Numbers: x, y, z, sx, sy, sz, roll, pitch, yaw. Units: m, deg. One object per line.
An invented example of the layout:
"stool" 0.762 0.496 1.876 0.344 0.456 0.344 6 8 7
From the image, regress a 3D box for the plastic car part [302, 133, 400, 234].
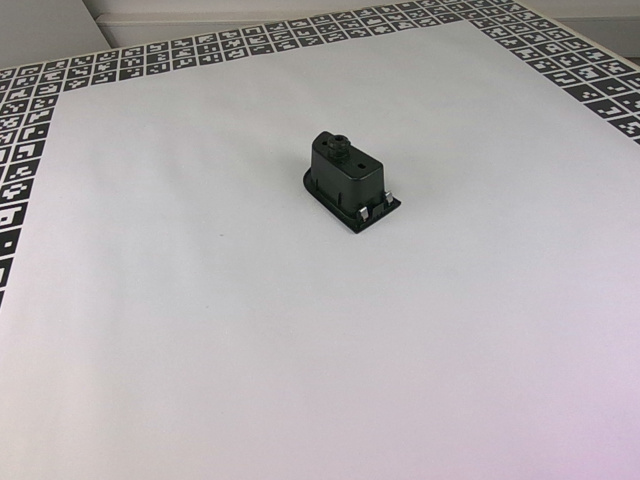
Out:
"plastic car part" 0.025 -0.074 0.456 0.065 0.071 0.117 -32 58 -24
